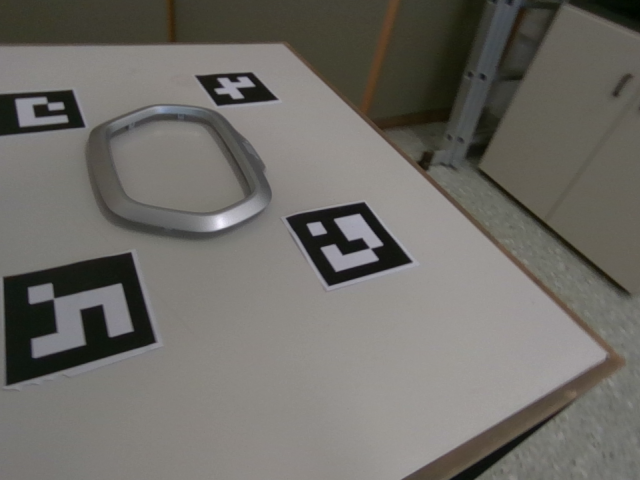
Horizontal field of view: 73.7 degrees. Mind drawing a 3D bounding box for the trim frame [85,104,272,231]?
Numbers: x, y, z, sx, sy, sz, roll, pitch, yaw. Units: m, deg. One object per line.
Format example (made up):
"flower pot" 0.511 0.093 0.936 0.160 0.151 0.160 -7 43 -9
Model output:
"trim frame" -0.155 -0.090 0.476 0.182 0.027 0.250 -17 48 -25
